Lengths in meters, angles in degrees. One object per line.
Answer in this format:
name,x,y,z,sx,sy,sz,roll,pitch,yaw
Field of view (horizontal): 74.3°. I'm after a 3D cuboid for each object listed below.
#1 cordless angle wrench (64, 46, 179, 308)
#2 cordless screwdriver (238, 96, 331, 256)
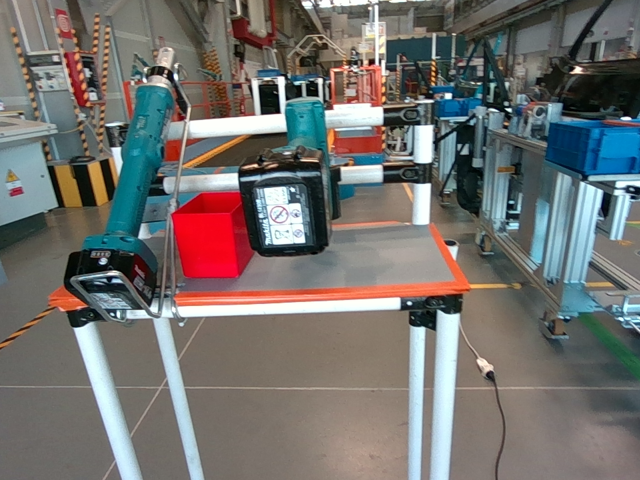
cordless angle wrench,-0.246,-0.119,0.590,0.074,0.421,0.098,1,-26,0
cordless screwdriver,-0.020,-0.060,0.482,0.074,0.159,0.248,-2,29,6
